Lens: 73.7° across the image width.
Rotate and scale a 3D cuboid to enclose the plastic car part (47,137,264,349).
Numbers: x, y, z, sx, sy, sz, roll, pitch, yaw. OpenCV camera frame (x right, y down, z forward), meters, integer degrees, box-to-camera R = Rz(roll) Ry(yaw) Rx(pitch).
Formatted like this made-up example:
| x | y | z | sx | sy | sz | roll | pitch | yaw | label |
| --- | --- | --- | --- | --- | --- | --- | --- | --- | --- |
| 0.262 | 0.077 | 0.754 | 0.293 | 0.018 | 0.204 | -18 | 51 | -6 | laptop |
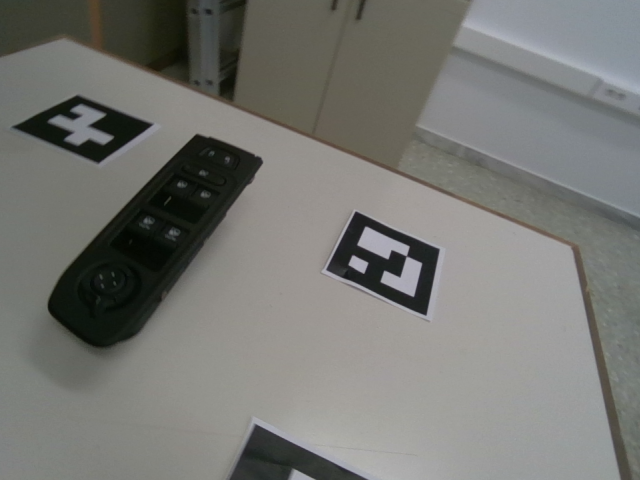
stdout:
| x | y | z | sx | sy | sz | roll | pitch | yaw | label |
| --- | --- | --- | --- | --- | --- | --- | --- | --- | --- |
| -0.118 | -0.001 | 0.326 | 0.066 | 0.067 | 0.202 | 28 | 44 | -1 | plastic car part |
